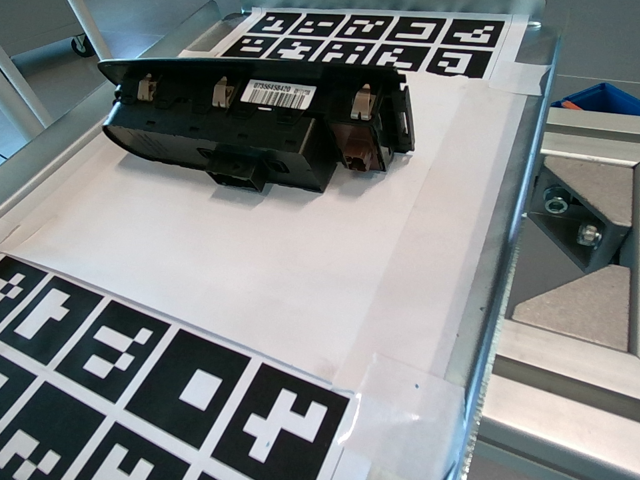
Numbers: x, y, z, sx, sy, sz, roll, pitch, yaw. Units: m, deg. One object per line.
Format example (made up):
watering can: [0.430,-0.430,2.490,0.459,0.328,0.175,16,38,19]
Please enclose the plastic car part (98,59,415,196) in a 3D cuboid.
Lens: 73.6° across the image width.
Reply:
plastic car part: [-0.052,-0.063,0.252,0.204,0.067,0.066,16,-12,23]
